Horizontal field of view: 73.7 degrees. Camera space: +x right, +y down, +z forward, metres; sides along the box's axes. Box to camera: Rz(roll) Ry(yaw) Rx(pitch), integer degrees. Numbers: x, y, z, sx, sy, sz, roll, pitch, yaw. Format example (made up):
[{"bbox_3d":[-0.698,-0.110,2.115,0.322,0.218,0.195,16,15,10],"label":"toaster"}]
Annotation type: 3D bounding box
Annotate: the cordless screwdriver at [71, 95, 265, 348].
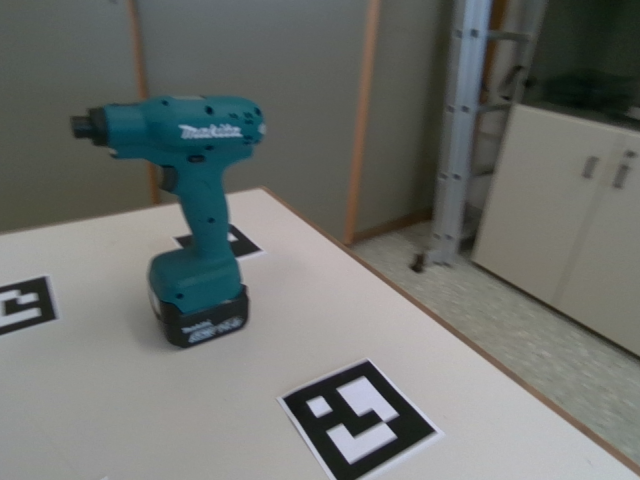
[{"bbox_3d":[-0.140,-0.012,0.419,0.157,0.249,0.075,-10,31,-31],"label":"cordless screwdriver"}]
